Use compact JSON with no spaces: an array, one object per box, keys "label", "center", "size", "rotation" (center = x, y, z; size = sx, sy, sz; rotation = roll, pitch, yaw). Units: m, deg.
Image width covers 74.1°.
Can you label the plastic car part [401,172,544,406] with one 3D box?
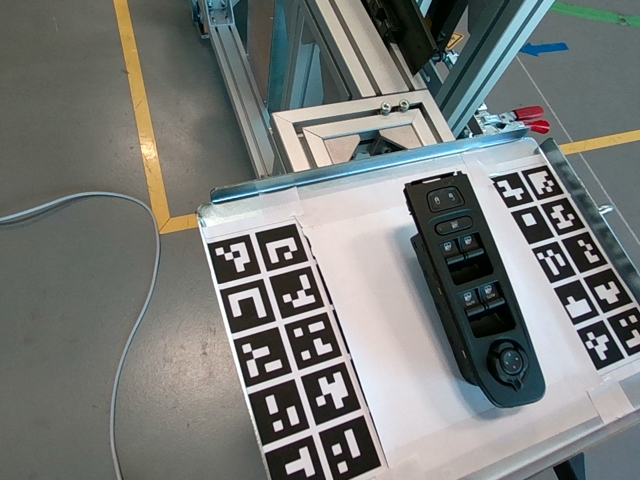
[{"label":"plastic car part","center":[0.125,0.045,0.376],"size":[0.066,0.203,0.067],"rotation":[-13,-17,-25]}]
